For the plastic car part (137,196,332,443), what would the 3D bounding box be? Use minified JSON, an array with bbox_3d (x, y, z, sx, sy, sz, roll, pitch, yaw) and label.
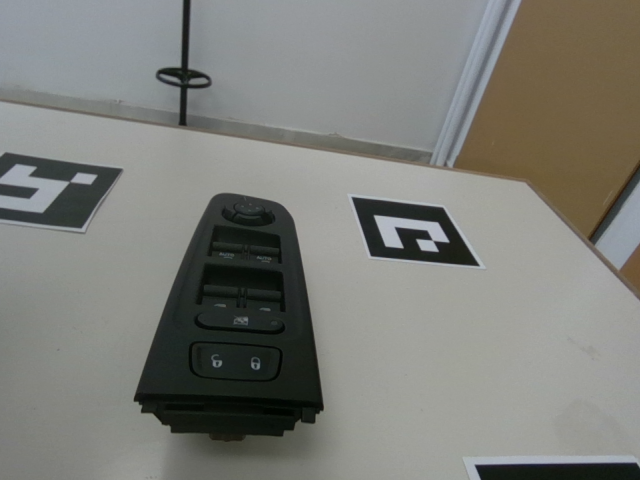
[{"bbox_3d":[-0.040,0.030,0.241,0.066,0.067,0.203,-2,30,-7],"label":"plastic car part"}]
